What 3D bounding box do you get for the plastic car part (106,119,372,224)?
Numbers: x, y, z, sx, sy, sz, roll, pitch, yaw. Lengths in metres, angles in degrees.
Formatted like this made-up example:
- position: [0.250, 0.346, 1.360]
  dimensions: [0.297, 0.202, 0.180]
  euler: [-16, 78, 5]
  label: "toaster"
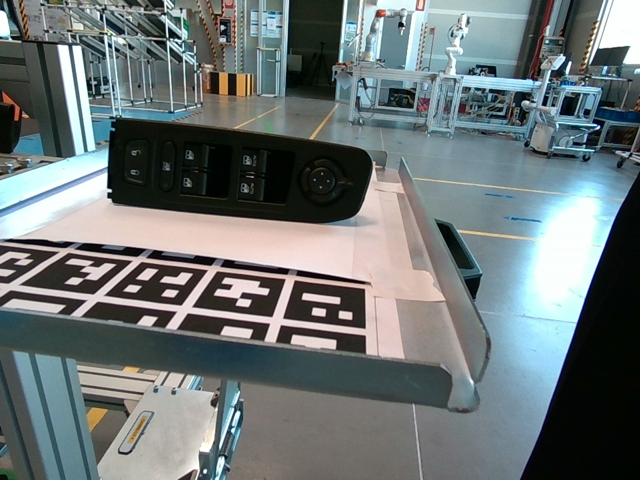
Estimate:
- position: [-0.062, -0.049, 0.347]
  dimensions: [0.204, 0.066, 0.067]
  euler: [6, -4, 6]
  label: "plastic car part"
